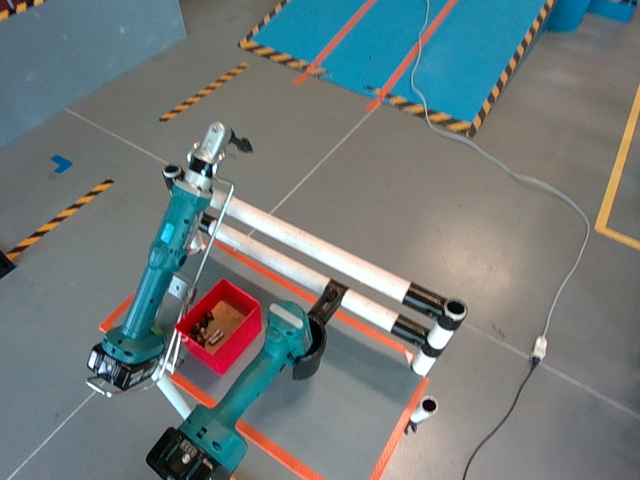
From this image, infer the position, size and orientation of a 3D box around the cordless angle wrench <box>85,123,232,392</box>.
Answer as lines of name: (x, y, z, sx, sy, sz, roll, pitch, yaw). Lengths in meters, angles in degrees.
cordless angle wrench: (-0.229, 0.021, 0.644, 0.074, 0.423, 0.098, 25, 6, 12)

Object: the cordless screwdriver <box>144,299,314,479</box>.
cordless screwdriver: (-0.091, 0.204, 0.542, 0.074, 0.248, 0.159, 28, -26, 22)
